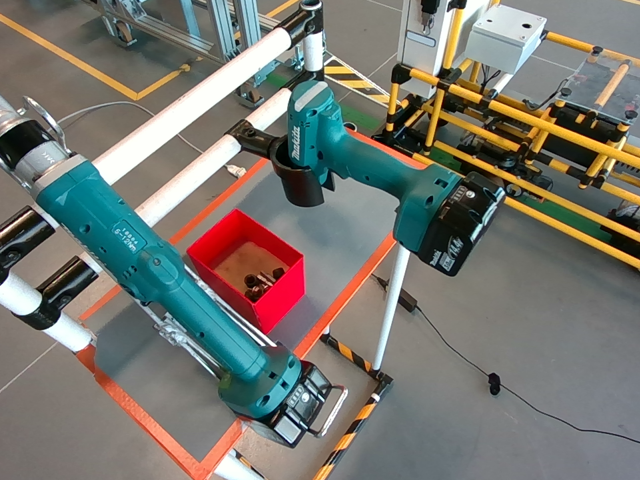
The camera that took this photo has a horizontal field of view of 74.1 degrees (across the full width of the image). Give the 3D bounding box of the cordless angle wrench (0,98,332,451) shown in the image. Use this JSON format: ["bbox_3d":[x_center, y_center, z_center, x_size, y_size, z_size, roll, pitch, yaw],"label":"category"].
[{"bbox_3d":[-0.156,0.028,0.387,0.098,0.423,0.074,-21,24,51],"label":"cordless angle wrench"}]

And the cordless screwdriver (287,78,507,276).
[{"bbox_3d":[0.064,-0.059,0.477,0.249,0.074,0.159,36,-24,15],"label":"cordless screwdriver"}]
